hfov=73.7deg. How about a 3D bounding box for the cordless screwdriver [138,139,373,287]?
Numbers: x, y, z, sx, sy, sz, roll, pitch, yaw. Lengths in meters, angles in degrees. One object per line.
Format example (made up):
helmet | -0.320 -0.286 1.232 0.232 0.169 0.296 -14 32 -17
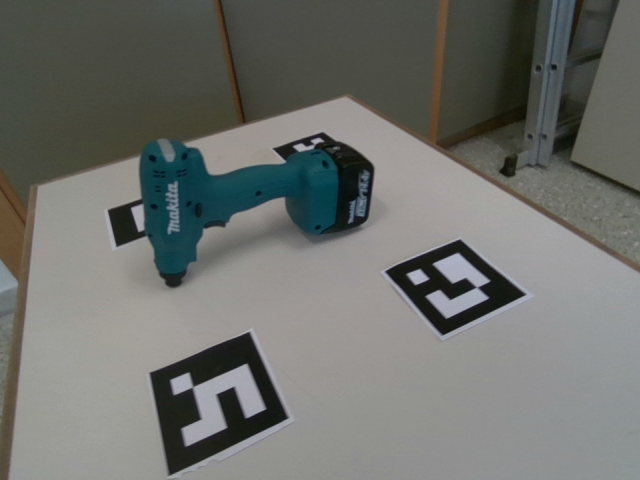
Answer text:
cordless screwdriver | -0.067 -0.032 0.481 0.246 0.159 0.075 -8 32 -24
